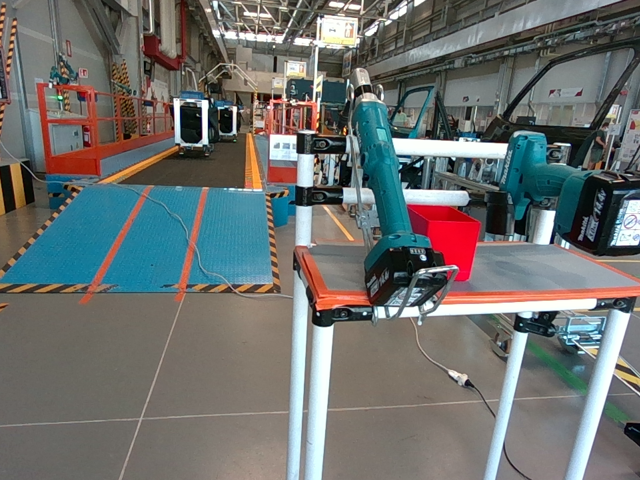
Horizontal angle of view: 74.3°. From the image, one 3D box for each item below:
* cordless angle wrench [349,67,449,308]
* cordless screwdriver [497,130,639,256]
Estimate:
[{"bbox_3d":[0.086,-0.111,0.623,0.074,0.421,0.098,5,-32,-19],"label":"cordless angle wrench"},{"bbox_3d":[0.329,-0.050,0.588,0.074,0.159,0.248,-1,26,-9],"label":"cordless screwdriver"}]
